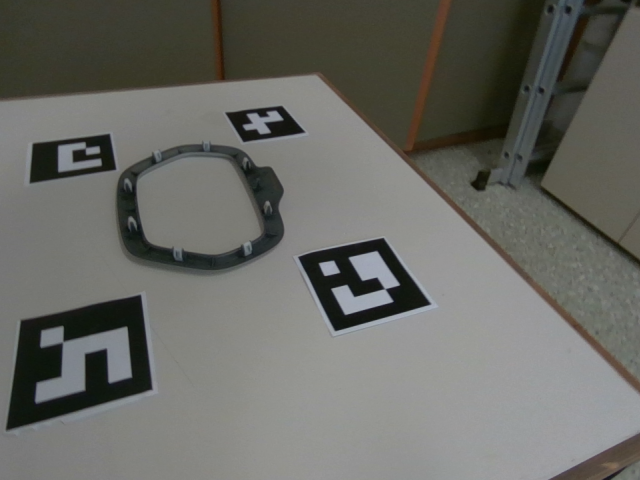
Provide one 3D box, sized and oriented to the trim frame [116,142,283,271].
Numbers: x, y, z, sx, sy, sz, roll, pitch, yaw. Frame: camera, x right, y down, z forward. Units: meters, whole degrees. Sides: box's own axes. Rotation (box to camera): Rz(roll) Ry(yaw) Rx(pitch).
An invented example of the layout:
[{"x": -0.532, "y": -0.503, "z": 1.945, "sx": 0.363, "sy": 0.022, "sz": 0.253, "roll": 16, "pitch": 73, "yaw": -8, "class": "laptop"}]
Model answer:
[{"x": -0.138, "y": -0.052, "z": 0.496, "sx": 0.183, "sy": 0.027, "sz": 0.250, "roll": -11, "pitch": 42, "yaw": -19, "class": "trim frame"}]
